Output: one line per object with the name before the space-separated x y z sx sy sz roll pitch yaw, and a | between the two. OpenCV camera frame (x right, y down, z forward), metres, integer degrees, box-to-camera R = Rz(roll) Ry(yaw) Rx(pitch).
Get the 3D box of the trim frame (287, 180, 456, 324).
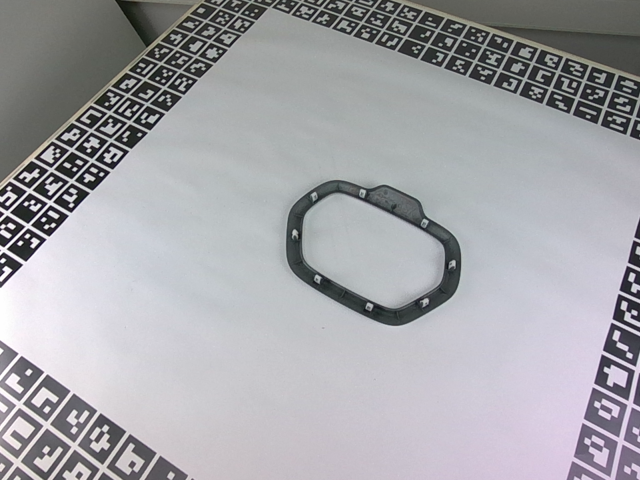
trim frame | 0.069 0.007 0.592 0.249 0.183 0.027 28 -20 12
